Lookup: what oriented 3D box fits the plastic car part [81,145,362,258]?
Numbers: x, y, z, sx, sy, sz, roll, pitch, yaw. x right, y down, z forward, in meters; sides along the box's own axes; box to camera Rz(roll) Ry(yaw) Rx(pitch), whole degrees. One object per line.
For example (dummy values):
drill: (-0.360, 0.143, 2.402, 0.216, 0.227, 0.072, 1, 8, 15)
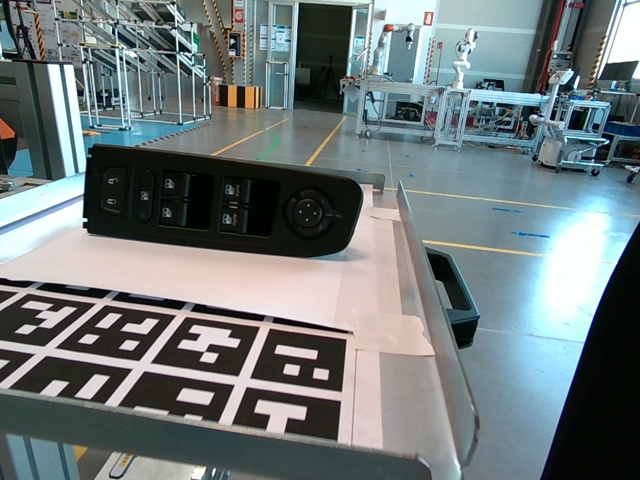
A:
plastic car part: (-0.071, -0.024, 0.329, 0.204, 0.066, 0.067, 6, -5, 7)
